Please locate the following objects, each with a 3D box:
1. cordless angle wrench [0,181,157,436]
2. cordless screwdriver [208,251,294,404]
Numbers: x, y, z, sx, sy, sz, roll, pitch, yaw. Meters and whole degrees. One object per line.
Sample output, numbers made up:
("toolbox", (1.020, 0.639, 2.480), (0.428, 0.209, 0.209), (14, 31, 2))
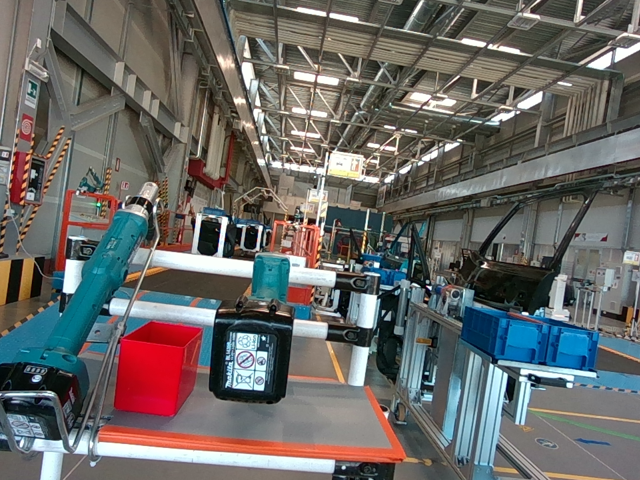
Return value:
("cordless angle wrench", (-0.307, 0.048, 0.602), (0.074, 0.098, 0.421), (11, 43, -8))
("cordless screwdriver", (-0.071, 0.113, 0.508), (0.074, 0.159, 0.248), (6, 10, -3))
